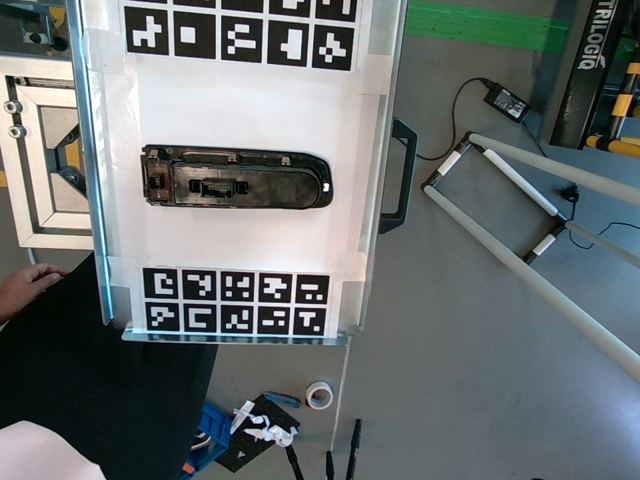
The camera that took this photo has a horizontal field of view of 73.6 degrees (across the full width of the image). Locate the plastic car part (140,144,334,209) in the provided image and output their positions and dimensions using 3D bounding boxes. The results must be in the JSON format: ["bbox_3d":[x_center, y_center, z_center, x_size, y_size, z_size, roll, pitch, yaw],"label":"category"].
[{"bbox_3d":[-0.083,-0.061,0.439,0.203,0.066,0.067,1,14,-7],"label":"plastic car part"}]
